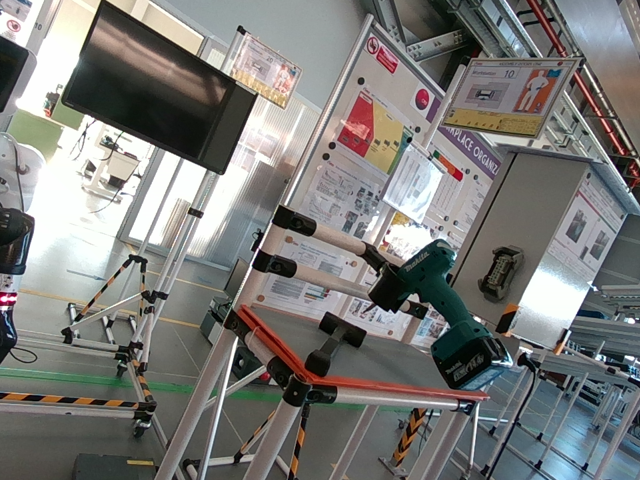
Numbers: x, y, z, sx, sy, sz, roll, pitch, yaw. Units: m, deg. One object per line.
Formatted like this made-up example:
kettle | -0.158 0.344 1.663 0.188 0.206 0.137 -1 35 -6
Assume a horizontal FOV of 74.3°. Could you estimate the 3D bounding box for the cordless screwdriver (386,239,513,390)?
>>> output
cordless screwdriver | 0.201 0.135 0.728 0.074 0.248 0.159 20 -52 -40
